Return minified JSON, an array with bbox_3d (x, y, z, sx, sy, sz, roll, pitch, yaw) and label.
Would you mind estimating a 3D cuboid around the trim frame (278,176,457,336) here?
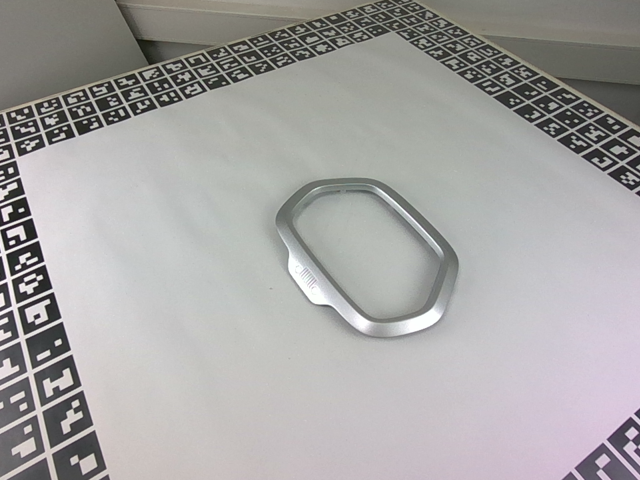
[{"bbox_3d":[0.052,0.007,0.529,0.183,0.249,0.027,-30,-29,-16],"label":"trim frame"}]
